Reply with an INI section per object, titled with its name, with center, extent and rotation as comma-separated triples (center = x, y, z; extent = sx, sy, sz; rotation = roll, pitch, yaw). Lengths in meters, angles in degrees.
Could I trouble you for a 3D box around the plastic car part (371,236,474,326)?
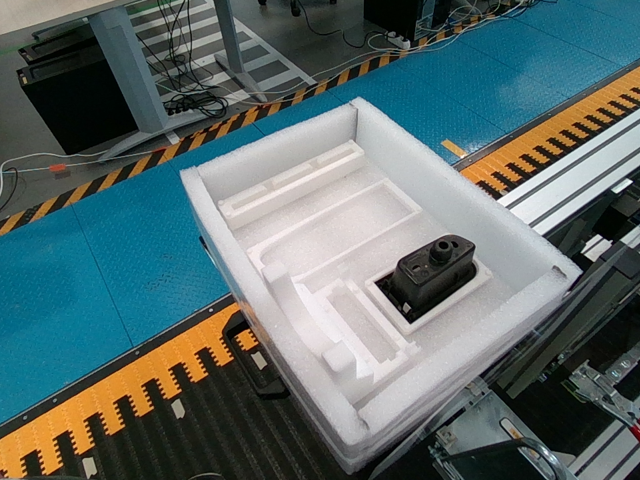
[plastic car part]
center = 0.126, 0.031, 0.480
extent = 0.116, 0.066, 0.071
rotation = -29, -33, -15
